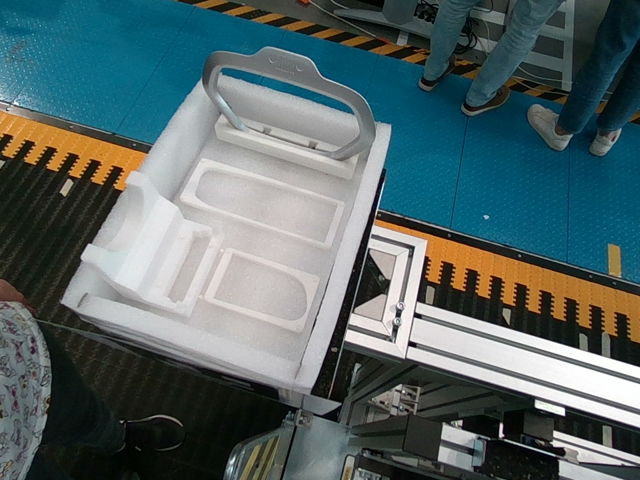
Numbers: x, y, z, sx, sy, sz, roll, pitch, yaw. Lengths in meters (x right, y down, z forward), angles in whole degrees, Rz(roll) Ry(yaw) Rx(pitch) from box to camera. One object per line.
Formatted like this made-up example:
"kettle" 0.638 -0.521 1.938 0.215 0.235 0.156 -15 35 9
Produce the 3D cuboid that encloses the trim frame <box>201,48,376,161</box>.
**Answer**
"trim frame" -0.044 -0.177 0.576 0.249 0.027 0.184 19 -20 5
